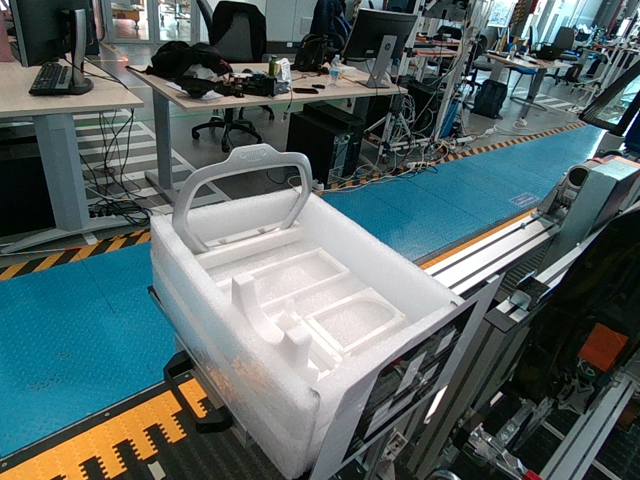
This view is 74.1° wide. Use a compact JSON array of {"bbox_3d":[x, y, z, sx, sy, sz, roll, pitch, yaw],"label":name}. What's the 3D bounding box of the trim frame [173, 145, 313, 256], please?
[{"bbox_3d":[-0.112,-0.061,0.670,0.247,0.185,0.027,-17,47,-32],"label":"trim frame"}]
